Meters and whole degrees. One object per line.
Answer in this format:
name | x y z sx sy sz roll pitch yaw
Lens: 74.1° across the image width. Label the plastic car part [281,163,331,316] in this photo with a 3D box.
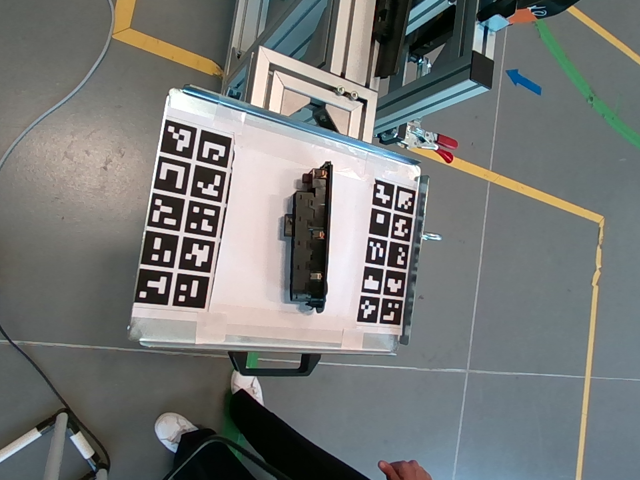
plastic car part | -0.017 0.003 0.563 0.068 0.203 0.068 -2 0 -17
